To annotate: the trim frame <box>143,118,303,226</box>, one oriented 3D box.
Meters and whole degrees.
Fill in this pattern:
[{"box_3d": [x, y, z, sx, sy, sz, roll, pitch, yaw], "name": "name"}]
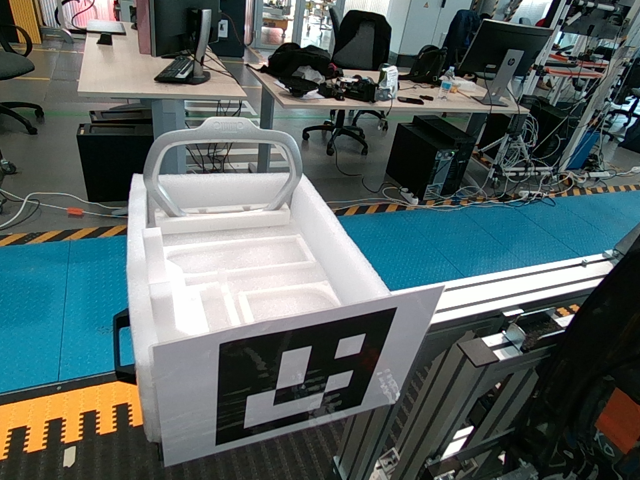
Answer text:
[{"box_3d": [-0.145, -0.100, 0.665, 0.247, 0.184, 0.027, -6, 41, -19], "name": "trim frame"}]
